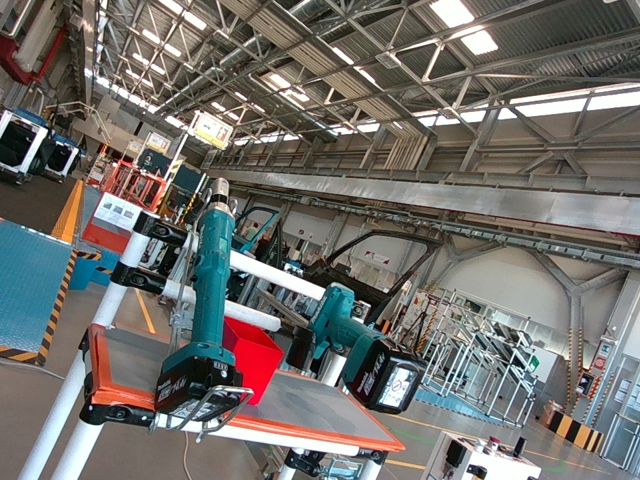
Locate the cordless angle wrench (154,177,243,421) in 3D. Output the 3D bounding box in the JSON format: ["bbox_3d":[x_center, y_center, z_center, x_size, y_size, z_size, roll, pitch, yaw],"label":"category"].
[{"bbox_3d":[-0.167,0.046,0.646,0.098,0.422,0.074,-36,-49,29],"label":"cordless angle wrench"}]

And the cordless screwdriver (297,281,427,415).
[{"bbox_3d":[0.044,0.181,0.673,0.074,0.159,0.249,25,6,-30],"label":"cordless screwdriver"}]
